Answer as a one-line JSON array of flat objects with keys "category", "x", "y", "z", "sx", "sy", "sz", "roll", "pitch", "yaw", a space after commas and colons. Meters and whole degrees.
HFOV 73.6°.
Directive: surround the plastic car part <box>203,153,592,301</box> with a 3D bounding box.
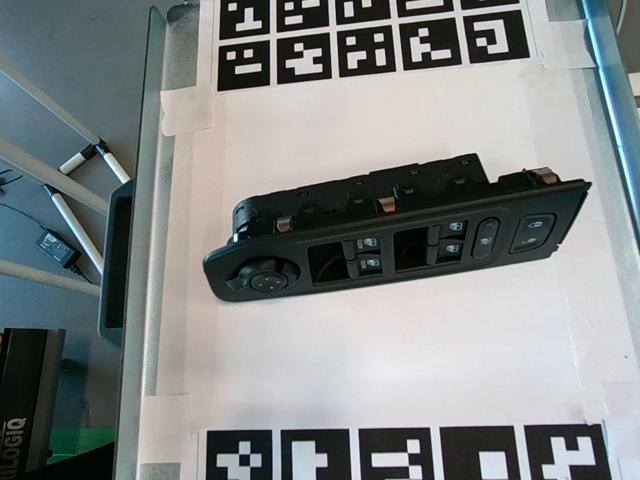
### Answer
[{"category": "plastic car part", "x": 0.031, "y": -0.010, "z": 0.244, "sx": 0.203, "sy": 0.067, "sz": 0.066, "roll": -14, "pitch": -28, "yaw": 3}]
